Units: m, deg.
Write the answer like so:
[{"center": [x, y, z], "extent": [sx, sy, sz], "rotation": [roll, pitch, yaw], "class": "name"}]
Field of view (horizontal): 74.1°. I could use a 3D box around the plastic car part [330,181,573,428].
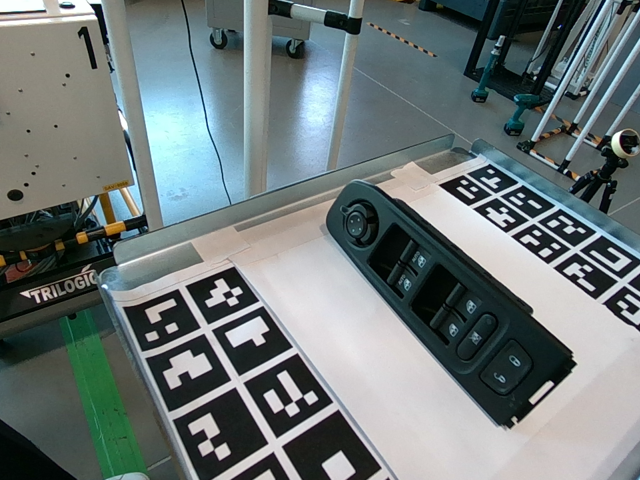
[{"center": [0.082, 0.022, 0.303], "extent": [0.066, 0.066, 0.203], "rotation": [-20, 48, -33], "class": "plastic car part"}]
